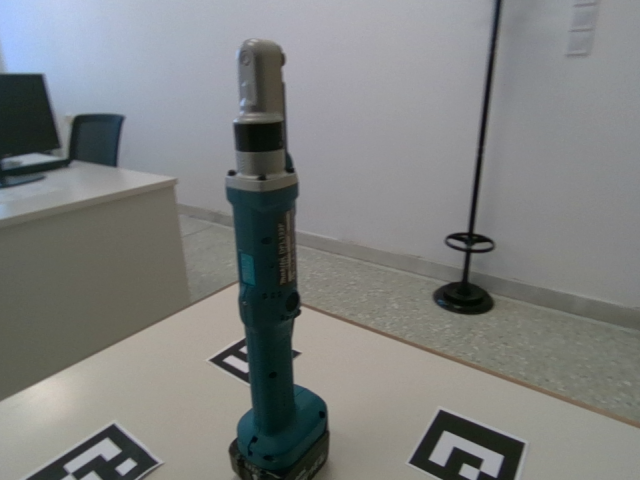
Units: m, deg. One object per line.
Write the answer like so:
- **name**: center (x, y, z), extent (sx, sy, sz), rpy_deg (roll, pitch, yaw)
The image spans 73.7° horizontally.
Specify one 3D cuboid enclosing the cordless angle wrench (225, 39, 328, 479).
- **cordless angle wrench**: center (-0.046, 0.049, 0.391), extent (0.075, 0.423, 0.097), rpy_deg (14, 25, 35)
